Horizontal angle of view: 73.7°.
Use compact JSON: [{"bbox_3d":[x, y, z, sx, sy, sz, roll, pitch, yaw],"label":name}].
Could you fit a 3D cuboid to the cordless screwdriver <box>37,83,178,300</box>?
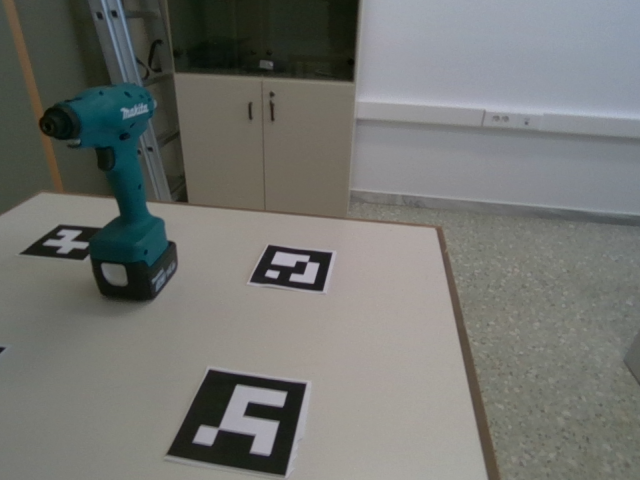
[{"bbox_3d":[-0.236,-0.044,0.490,0.074,0.249,0.159,6,25,6],"label":"cordless screwdriver"}]
